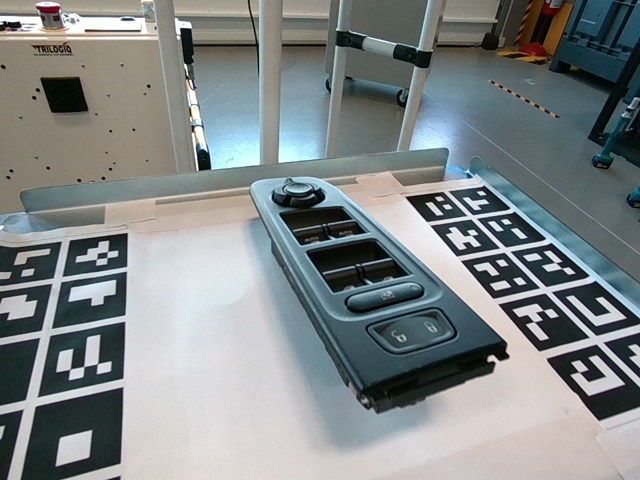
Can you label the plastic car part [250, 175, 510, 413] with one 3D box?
[{"bbox_3d":[0.011,0.017,0.248,0.066,0.067,0.203,-17,39,-14],"label":"plastic car part"}]
